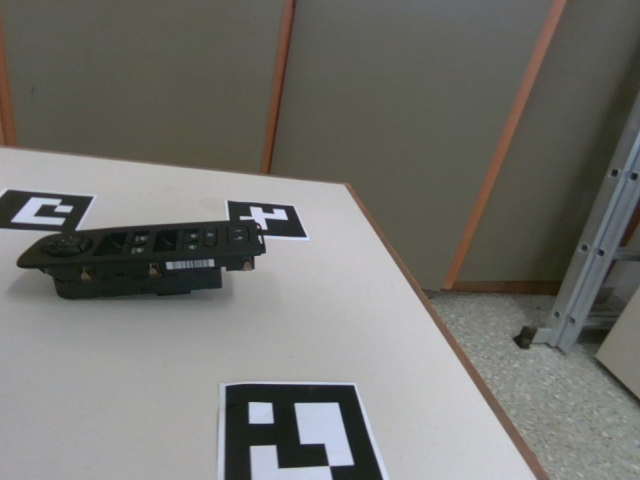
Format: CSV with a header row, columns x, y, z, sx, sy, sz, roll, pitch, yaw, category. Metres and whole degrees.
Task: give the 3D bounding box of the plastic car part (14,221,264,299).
x,y,z,sx,sy,sz,roll,pitch,yaw,category
-0.157,0.019,0.394,0.202,0.067,0.066,0,36,-14,plastic car part
